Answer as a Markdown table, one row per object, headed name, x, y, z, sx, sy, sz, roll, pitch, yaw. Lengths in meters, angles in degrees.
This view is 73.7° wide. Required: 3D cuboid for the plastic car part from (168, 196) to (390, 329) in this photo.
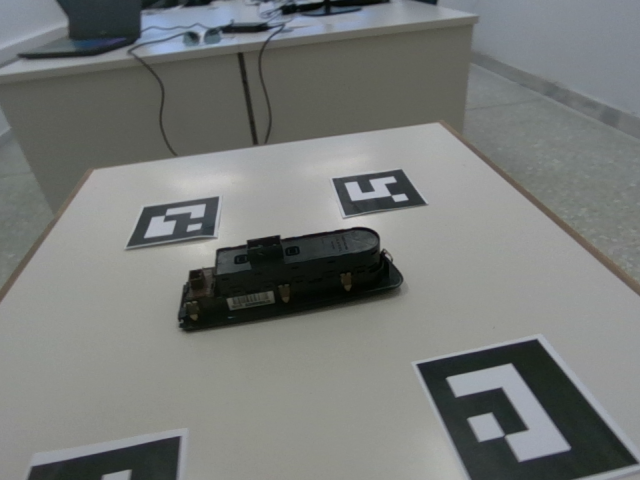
| name | x | y | z | sx | sy | sz | roll | pitch | yaw |
| --- | --- | --- | --- | --- | --- | --- | --- | --- | --- |
| plastic car part | -0.032 | 0.006 | 0.379 | 0.202 | 0.066 | 0.067 | -18 | -26 | -15 |
